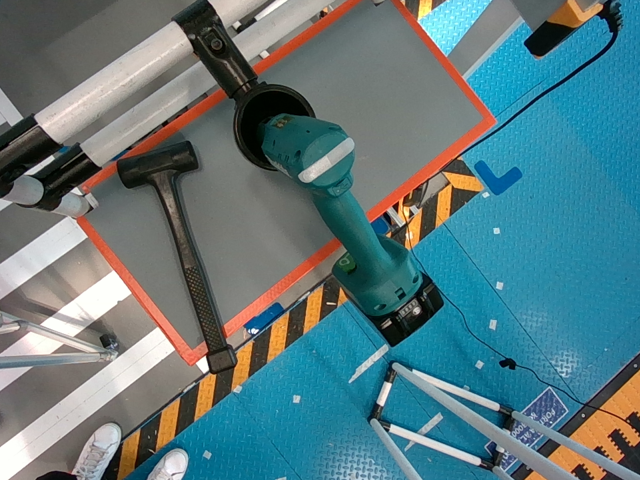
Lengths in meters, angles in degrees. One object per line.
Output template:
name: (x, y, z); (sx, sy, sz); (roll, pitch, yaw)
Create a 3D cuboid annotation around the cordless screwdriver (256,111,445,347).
cordless screwdriver: (0.022, -0.016, 0.423); (0.074, 0.249, 0.159); (-37, 32, -6)
